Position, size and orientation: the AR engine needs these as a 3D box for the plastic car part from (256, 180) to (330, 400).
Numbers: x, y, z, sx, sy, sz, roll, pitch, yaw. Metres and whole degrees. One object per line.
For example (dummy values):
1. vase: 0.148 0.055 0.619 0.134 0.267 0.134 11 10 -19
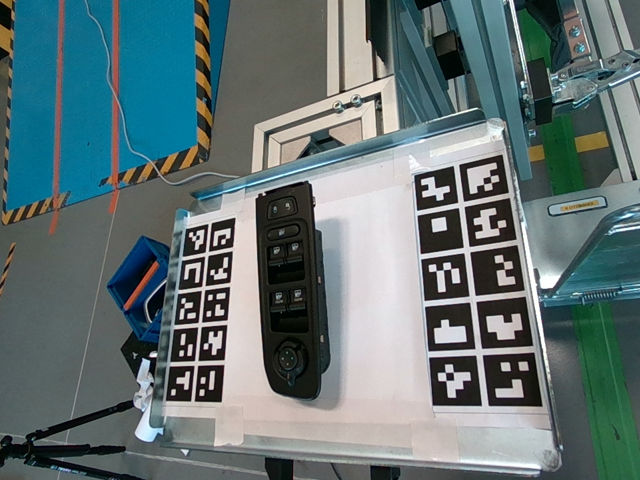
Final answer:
1. plastic car part: -0.024 0.050 0.423 0.067 0.202 0.067 -9 -18 19
